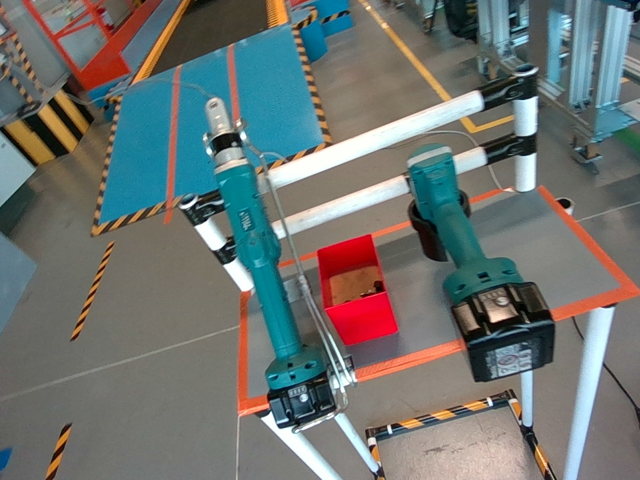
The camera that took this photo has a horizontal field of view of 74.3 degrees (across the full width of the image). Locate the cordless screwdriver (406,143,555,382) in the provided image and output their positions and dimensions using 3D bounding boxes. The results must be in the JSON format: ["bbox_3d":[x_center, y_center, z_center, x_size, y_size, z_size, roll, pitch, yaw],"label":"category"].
[{"bbox_3d":[0.158,0.026,0.460,0.074,0.248,0.159,-19,-41,11],"label":"cordless screwdriver"}]

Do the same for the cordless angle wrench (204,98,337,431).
[{"bbox_3d":[-0.079,0.012,0.538,0.074,0.422,0.098,-18,-8,-2],"label":"cordless angle wrench"}]
